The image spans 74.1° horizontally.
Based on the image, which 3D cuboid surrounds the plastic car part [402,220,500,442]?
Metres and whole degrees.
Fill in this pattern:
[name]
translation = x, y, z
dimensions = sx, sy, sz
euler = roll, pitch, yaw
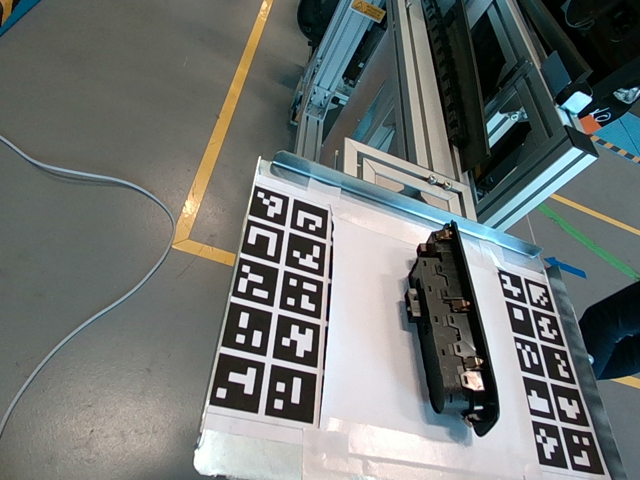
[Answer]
[plastic car part]
translation = 0.116, 0.075, 0.395
dimensions = 0.067, 0.202, 0.066
euler = 3, -37, -11
